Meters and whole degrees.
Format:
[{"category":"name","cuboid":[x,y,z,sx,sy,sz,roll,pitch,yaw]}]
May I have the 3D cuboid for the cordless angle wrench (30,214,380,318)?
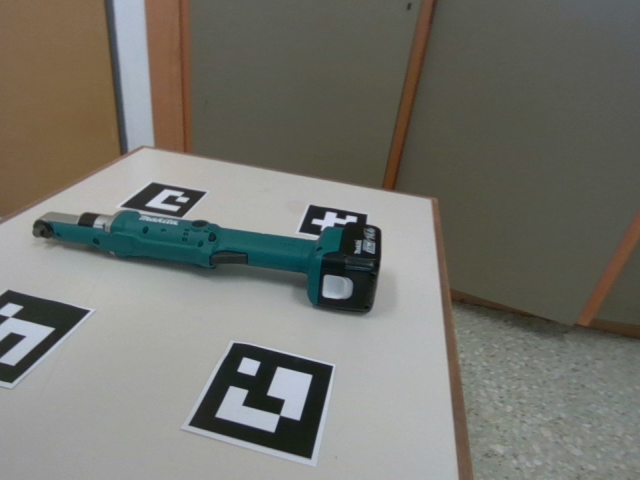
[{"category":"cordless angle wrench","cuboid":[-0.144,0.012,0.515,0.424,0.074,0.098,8,30,6]}]
